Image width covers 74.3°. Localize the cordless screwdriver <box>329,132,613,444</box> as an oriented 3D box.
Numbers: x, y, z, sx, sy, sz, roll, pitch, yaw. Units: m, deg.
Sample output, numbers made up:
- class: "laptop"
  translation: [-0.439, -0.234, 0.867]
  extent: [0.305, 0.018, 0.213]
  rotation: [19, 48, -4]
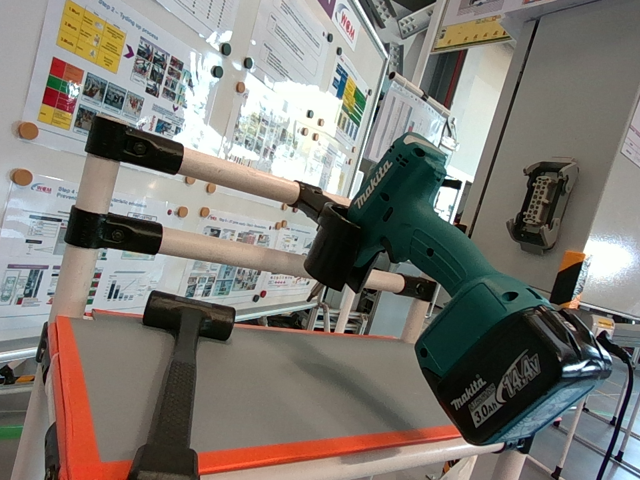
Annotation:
- class: "cordless screwdriver"
  translation: [0.088, 0.040, 0.352]
  extent: [0.074, 0.160, 0.248]
  rotation: [11, 38, -36]
